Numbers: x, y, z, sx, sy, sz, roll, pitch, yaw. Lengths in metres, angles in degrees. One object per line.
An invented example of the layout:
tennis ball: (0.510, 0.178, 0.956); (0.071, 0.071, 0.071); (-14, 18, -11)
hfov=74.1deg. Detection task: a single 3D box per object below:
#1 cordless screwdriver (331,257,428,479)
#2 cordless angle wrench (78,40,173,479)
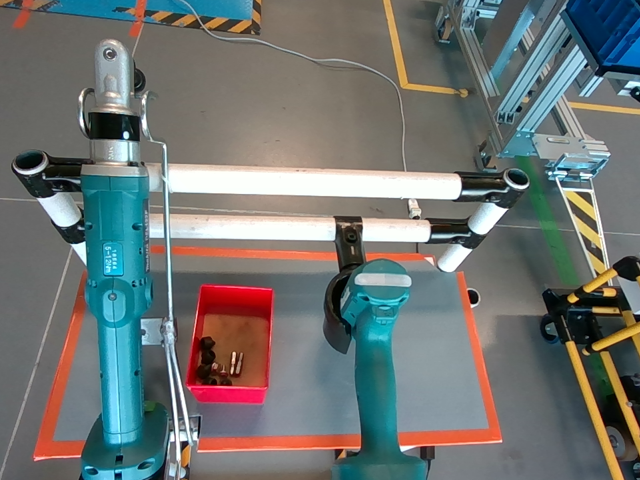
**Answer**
cordless screwdriver: (0.045, 0.155, 0.387); (0.074, 0.248, 0.159); (3, -25, -5)
cordless angle wrench: (-0.180, 0.045, 0.385); (0.074, 0.423, 0.098); (0, 10, -12)
